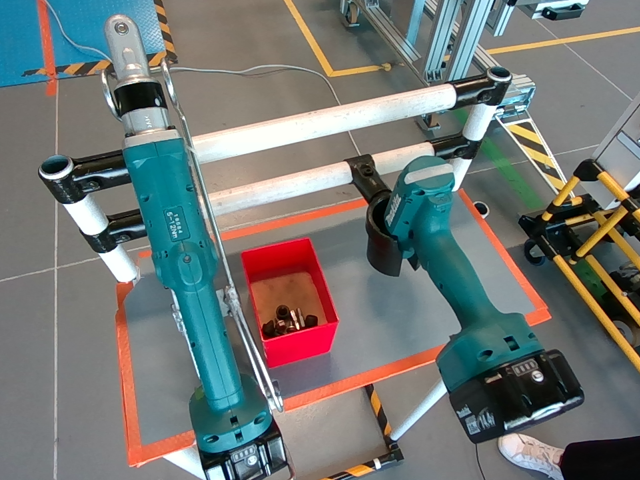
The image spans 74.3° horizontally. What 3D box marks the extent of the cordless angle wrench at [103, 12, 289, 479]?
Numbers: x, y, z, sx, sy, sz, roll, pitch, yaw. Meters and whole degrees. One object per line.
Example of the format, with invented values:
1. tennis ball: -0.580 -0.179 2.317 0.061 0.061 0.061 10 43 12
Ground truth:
1. cordless angle wrench: -0.119 0.017 0.382 0.074 0.423 0.098 -16 9 -15

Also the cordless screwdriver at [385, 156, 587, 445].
1. cordless screwdriver: 0.127 0.059 0.412 0.074 0.248 0.159 -15 -26 -10
